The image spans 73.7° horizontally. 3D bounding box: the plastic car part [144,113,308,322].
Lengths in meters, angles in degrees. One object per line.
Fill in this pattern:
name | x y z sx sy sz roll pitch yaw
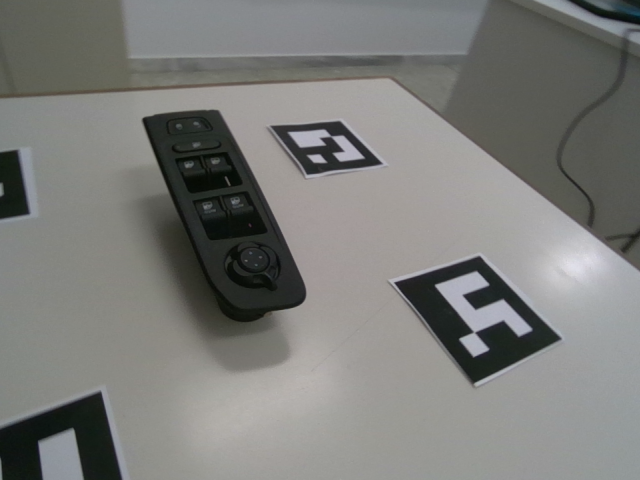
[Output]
plastic car part | -0.078 -0.018 0.323 0.066 0.067 0.204 -9 48 -32
